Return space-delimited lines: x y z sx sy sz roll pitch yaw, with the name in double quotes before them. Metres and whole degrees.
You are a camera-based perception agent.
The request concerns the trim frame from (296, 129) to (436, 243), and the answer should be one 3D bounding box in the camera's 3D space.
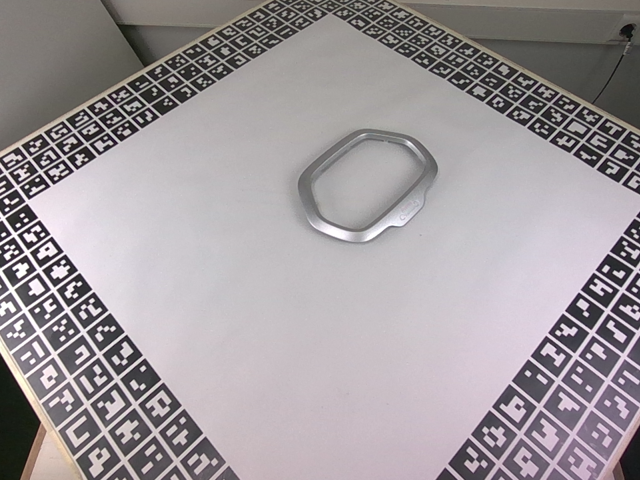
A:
"trim frame" 0.075 -0.094 0.685 0.184 0.247 0.027 37 -26 22
